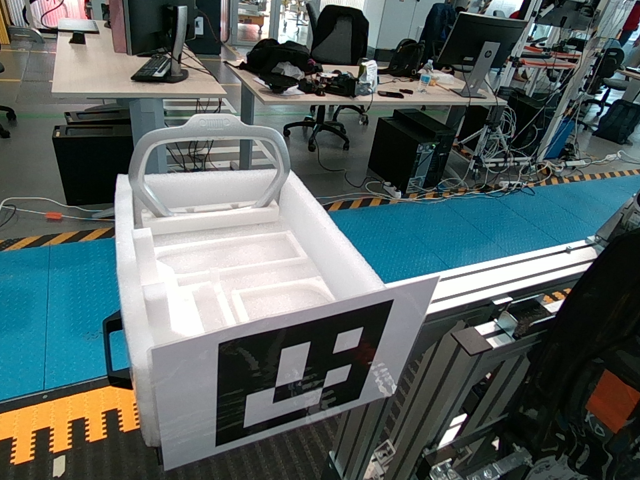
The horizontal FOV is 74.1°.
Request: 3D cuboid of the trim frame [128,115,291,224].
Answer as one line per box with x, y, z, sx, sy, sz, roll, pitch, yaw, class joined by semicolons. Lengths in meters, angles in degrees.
-0.164;-0.104;0.660;0.247;0.184;0.027;-6;42;-21;trim frame
